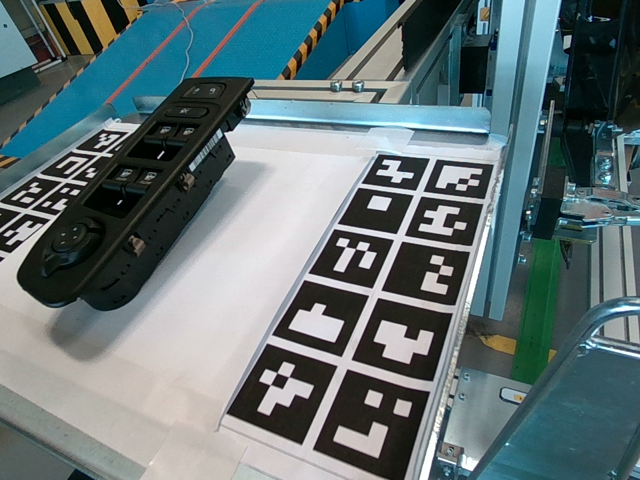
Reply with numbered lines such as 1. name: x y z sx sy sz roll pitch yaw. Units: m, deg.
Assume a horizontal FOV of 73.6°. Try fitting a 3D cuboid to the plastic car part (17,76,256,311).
1. plastic car part: -0.111 -0.034 0.289 0.066 0.202 0.067 15 -37 18
